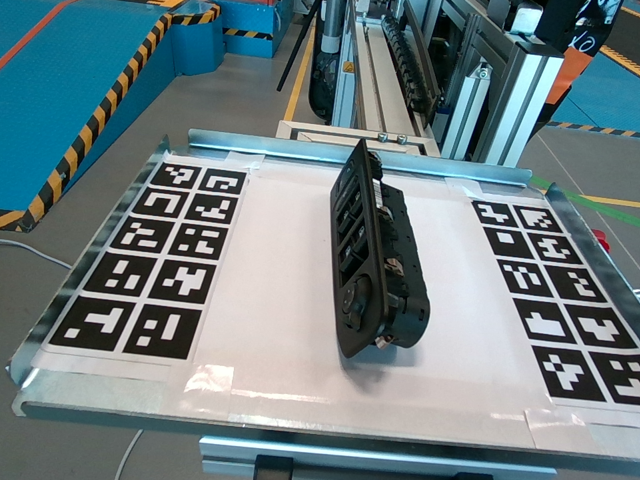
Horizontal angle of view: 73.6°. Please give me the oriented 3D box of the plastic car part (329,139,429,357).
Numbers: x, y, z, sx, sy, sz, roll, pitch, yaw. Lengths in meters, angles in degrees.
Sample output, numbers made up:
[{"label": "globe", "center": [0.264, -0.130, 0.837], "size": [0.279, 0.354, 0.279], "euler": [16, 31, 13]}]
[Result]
[{"label": "plastic car part", "center": [0.041, 0.006, 0.329], "size": [0.067, 0.067, 0.202], "euler": [29, 35, -17]}]
